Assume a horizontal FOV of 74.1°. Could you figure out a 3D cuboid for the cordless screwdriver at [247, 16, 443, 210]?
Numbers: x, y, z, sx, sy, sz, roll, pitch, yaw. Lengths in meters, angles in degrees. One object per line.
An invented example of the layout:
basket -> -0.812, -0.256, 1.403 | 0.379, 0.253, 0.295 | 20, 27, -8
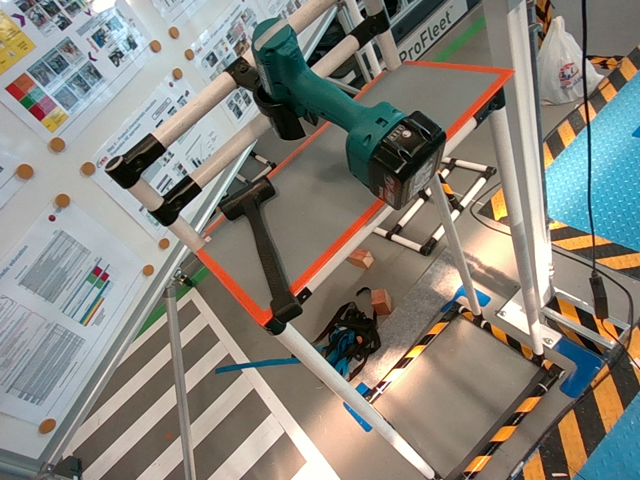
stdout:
cordless screwdriver -> 0.019, -0.138, 0.504 | 0.249, 0.074, 0.159 | 42, -10, 16
